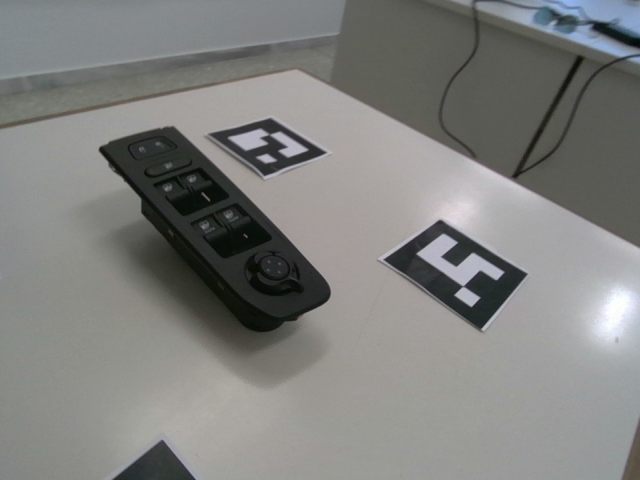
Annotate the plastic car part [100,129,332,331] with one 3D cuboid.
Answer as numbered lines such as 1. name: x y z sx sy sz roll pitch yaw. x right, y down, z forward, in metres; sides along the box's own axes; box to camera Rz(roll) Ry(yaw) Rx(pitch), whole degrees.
1. plastic car part: -0.082 -0.004 0.315 0.204 0.067 0.065 38 38 24
